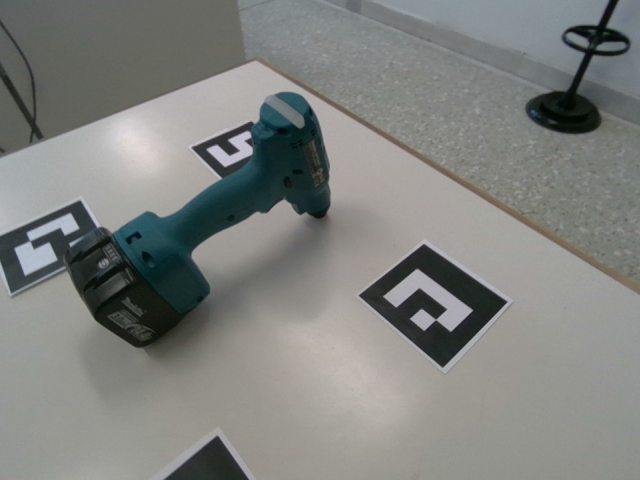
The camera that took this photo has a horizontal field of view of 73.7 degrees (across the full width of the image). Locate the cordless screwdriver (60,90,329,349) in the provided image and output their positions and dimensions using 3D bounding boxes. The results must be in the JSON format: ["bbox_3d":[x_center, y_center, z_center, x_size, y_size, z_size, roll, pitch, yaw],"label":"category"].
[{"bbox_3d":[-0.090,-0.009,0.400,0.075,0.248,0.158,43,-12,28],"label":"cordless screwdriver"}]
